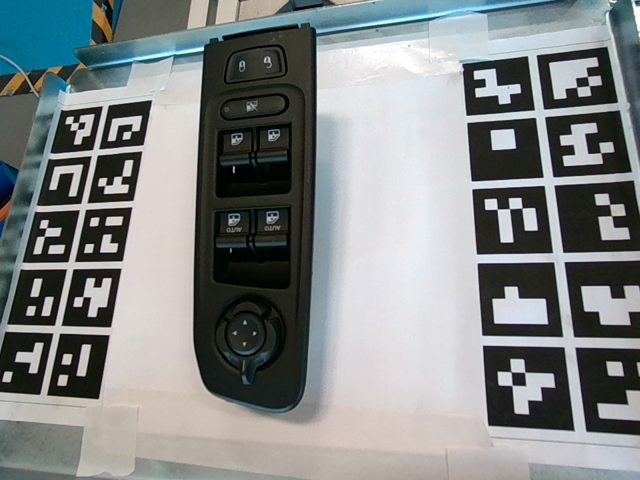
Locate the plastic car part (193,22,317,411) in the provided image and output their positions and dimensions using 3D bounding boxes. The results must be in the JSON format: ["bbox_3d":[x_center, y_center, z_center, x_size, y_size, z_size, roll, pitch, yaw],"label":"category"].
[{"bbox_3d":[-0.033,-0.014,0.241,0.066,0.202,0.067,-1,-14,6],"label":"plastic car part"}]
